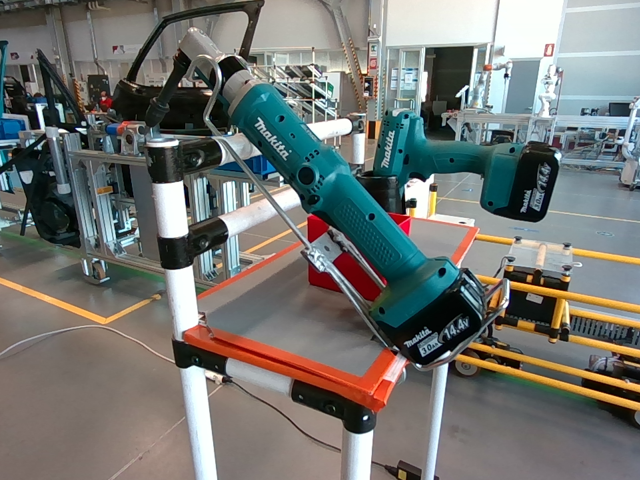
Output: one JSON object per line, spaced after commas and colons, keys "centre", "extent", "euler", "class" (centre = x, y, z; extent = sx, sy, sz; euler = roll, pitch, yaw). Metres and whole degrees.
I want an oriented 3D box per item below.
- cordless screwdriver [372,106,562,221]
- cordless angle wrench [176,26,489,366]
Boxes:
{"centre": [0.191, -0.086, 0.601], "extent": [0.249, 0.159, 0.074], "euler": [21, 26, 24], "class": "cordless screwdriver"}
{"centre": [-0.004, -0.066, 0.435], "extent": [0.098, 0.423, 0.074], "euler": [-45, -6, 28], "class": "cordless angle wrench"}
